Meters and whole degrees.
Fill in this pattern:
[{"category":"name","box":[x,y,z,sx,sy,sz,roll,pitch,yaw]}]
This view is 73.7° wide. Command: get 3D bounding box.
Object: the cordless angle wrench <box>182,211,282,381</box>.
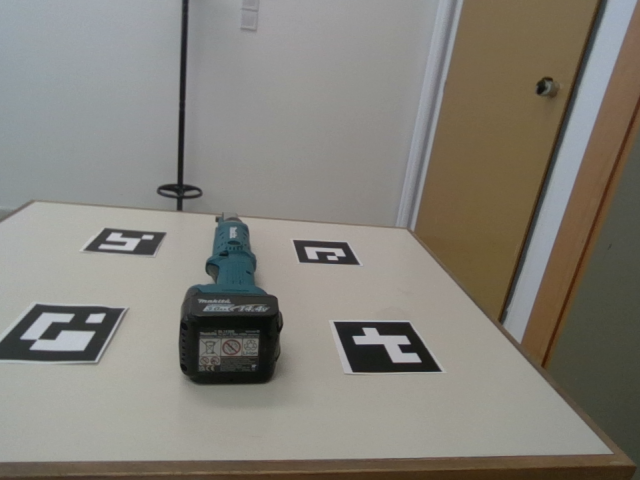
[{"category":"cordless angle wrench","box":[-0.125,0.031,0.599,0.097,0.074,0.424,4,20,-13]}]
